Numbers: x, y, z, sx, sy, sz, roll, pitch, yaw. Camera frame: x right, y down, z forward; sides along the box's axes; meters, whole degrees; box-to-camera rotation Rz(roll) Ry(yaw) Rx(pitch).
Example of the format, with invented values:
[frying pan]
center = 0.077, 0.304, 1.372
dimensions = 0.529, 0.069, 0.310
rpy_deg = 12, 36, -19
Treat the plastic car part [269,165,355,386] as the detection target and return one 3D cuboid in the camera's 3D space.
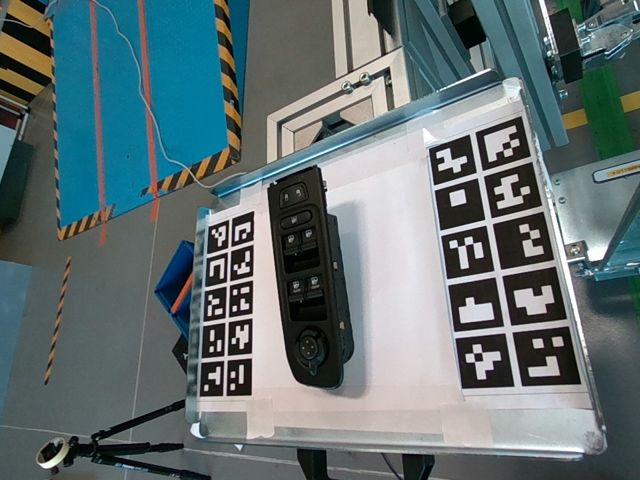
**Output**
[plastic car part]
center = -0.004, 0.036, 0.413
dimensions = 0.067, 0.202, 0.067
rpy_deg = -13, -19, 25
